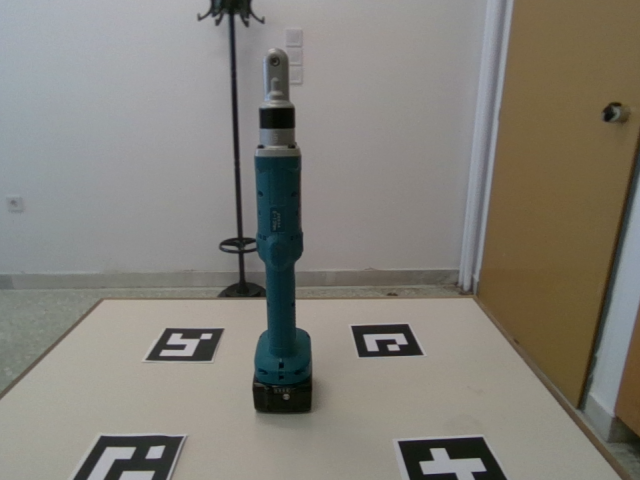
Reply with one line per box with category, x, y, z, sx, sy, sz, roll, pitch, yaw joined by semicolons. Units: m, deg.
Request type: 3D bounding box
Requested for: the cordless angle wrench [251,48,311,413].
cordless angle wrench;-0.048;0.003;0.505;0.074;0.423;0.098;0;17;-2
